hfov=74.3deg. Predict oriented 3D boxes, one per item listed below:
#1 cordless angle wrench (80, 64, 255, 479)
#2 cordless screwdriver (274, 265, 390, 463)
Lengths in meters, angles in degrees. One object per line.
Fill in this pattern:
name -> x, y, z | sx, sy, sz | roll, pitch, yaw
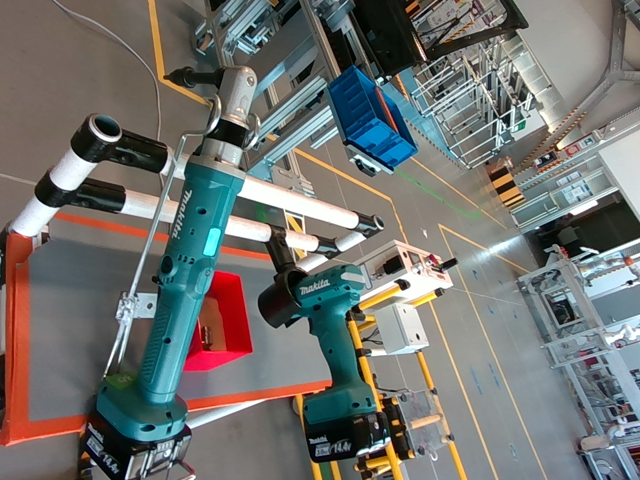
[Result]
cordless angle wrench -> -0.138, 0.028, 0.434 | 0.098, 0.423, 0.074 | 19, 3, 32
cordless screwdriver -> 0.003, 0.169, 0.591 | 0.159, 0.248, 0.074 | -23, -24, 35
